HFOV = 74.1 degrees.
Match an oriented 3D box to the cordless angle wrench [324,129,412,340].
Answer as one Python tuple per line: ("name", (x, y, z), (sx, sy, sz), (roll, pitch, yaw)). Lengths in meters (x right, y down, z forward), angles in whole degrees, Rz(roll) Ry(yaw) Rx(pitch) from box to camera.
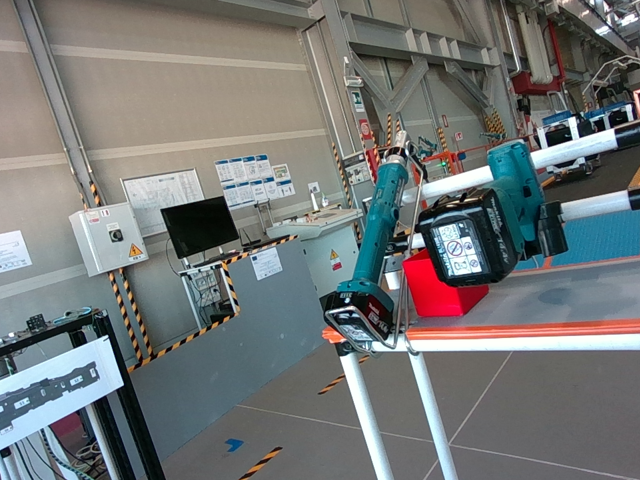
("cordless angle wrench", (0.110, -0.039, 0.740), (0.074, 0.421, 0.098), (-9, -39, 40))

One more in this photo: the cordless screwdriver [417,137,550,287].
("cordless screwdriver", (0.217, -0.018, 0.504), (0.074, 0.159, 0.248), (-15, 13, 44))
